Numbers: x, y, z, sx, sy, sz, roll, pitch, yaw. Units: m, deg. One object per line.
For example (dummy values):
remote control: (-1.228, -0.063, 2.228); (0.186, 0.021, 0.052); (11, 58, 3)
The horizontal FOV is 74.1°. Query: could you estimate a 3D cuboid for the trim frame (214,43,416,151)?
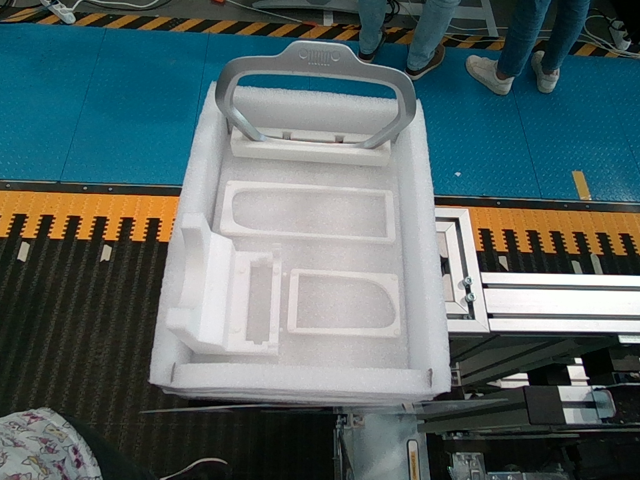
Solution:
trim frame: (-0.006, -0.165, 0.527); (0.249, 0.027, 0.184); (4, -20, -1)
